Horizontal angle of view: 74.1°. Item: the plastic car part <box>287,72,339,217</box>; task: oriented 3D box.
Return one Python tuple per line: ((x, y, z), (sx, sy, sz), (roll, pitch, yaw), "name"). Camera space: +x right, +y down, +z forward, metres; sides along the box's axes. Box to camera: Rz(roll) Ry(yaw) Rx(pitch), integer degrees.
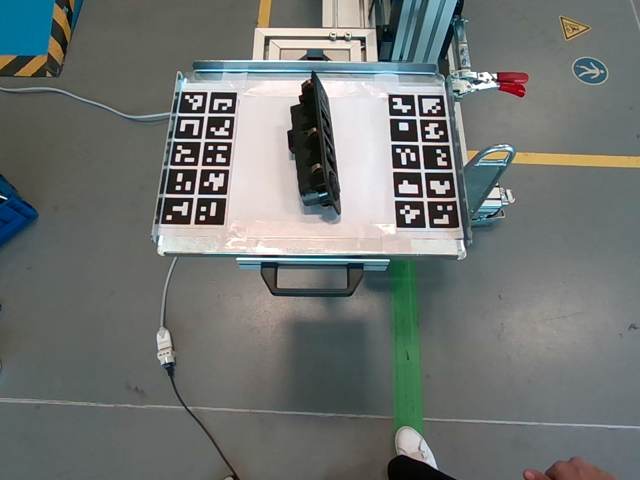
((-0.011, -0.126, 0.575), (0.067, 0.202, 0.066), (-13, -22, 8), "plastic car part")
